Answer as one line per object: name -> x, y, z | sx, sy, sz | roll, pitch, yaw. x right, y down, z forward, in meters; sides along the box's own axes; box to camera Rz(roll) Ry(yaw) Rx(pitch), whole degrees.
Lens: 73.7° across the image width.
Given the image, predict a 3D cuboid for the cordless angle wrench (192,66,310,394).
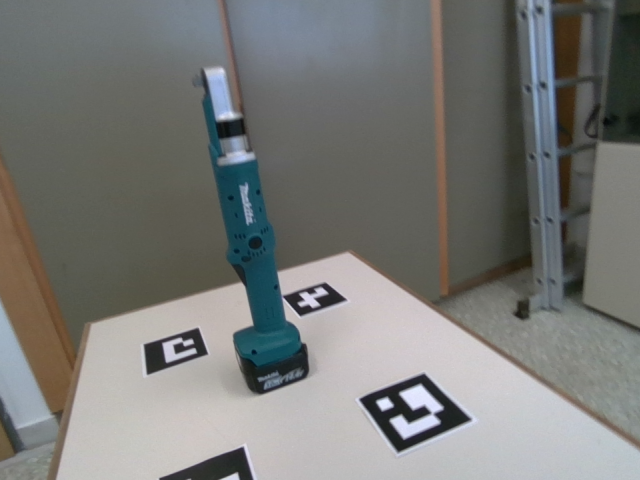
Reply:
cordless angle wrench -> -0.092, -0.001, 0.559 | 0.097, 0.422, 0.075 | -15, 20, -19
